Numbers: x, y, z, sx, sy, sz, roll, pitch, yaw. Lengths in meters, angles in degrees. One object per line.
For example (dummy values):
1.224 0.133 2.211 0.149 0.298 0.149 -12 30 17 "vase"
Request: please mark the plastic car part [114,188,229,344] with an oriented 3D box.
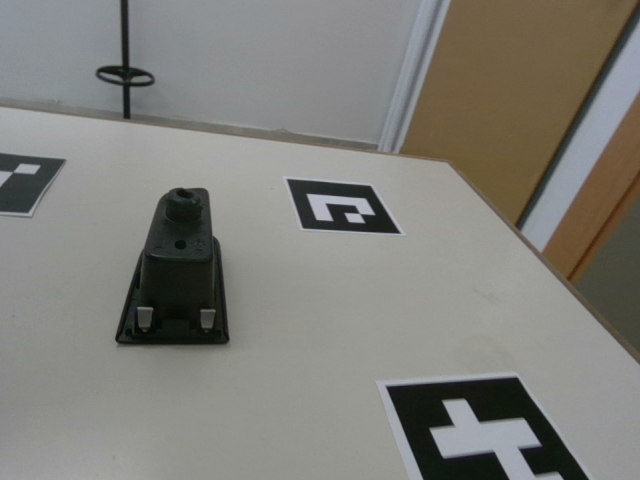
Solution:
-0.093 0.004 0.287 0.065 0.071 0.117 4 37 -16 "plastic car part"
